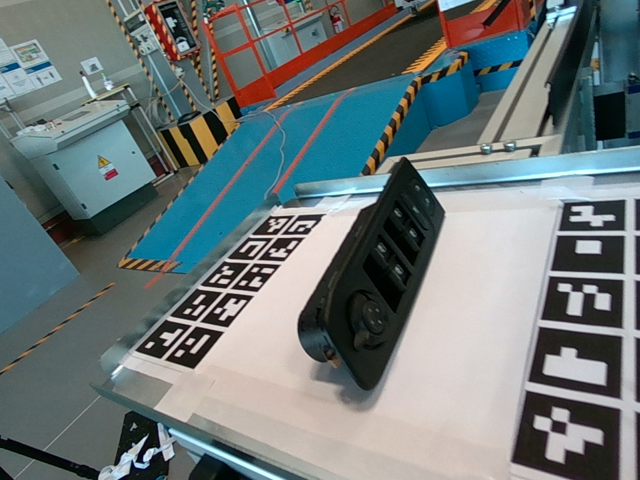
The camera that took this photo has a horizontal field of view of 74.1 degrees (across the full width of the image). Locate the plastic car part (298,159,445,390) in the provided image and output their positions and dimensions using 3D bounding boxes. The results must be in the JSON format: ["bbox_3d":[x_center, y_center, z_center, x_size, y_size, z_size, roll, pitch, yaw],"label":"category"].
[{"bbox_3d":[0.038,0.016,0.315,0.067,0.066,0.202,-21,24,34],"label":"plastic car part"}]
